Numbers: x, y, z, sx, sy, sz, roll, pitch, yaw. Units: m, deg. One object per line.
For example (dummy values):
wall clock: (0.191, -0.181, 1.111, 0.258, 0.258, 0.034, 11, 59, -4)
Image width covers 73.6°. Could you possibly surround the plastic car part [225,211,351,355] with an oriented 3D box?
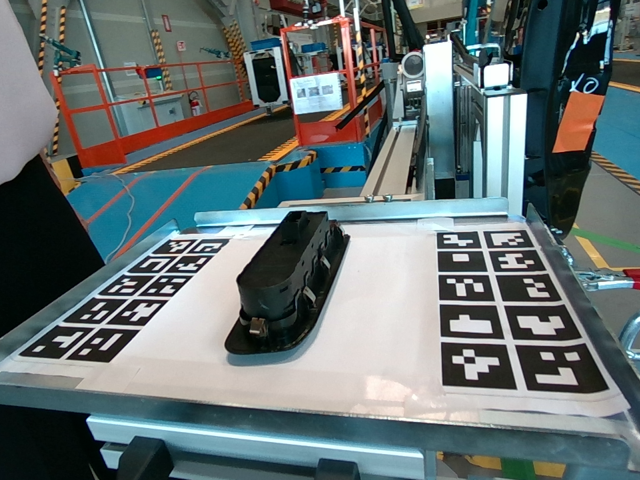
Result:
plastic car part: (-0.020, 0.018, 0.358, 0.066, 0.067, 0.202, 4, 28, 11)
